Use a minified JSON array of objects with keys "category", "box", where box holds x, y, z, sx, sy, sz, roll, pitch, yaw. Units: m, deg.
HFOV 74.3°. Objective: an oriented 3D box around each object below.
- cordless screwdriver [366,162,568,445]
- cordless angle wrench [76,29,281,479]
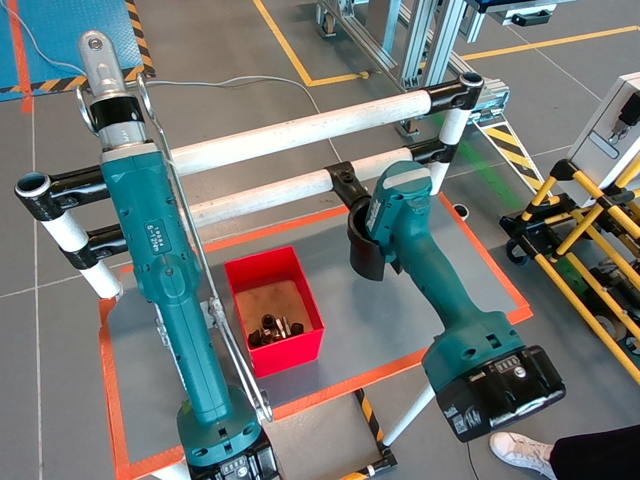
[{"category":"cordless screwdriver","box":[0.112,0.062,0.418,0.074,0.248,0.159,-17,-26,-13]},{"category":"cordless angle wrench","box":[-0.135,0.029,0.382,0.074,0.423,0.098,-18,9,-17]}]
